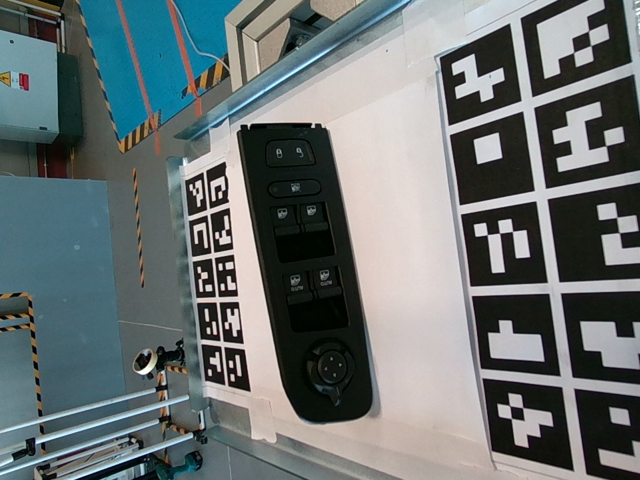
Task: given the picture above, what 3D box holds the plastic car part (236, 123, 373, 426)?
[{"bbox_3d":[-0.017,0.024,0.297,0.066,0.202,0.067,-6,-14,-33],"label":"plastic car part"}]
